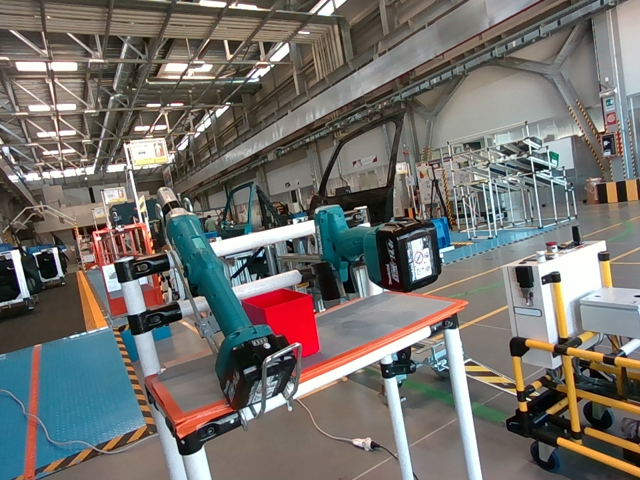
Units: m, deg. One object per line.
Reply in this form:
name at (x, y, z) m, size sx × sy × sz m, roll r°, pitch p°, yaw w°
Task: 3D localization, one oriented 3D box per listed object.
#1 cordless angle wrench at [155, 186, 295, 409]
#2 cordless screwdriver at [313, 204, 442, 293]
cordless angle wrench at (-0.177, 0.046, 0.645) m, size 0.074 × 0.098 × 0.422 m, roll -10°, pitch 46°, yaw -35°
cordless screwdriver at (0.073, 0.030, 0.668) m, size 0.074 × 0.159 × 0.249 m, roll -14°, pitch 15°, yaw -29°
